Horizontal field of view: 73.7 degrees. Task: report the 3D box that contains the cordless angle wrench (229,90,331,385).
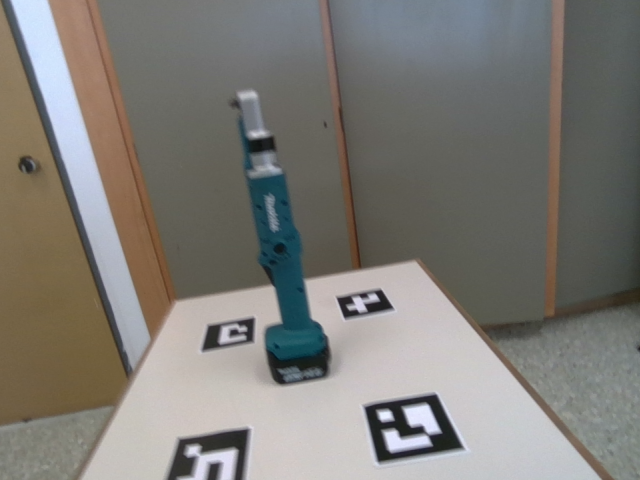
[{"bbox_3d":[-0.061,0.005,0.617,0.098,0.422,0.074,-10,17,-2],"label":"cordless angle wrench"}]
